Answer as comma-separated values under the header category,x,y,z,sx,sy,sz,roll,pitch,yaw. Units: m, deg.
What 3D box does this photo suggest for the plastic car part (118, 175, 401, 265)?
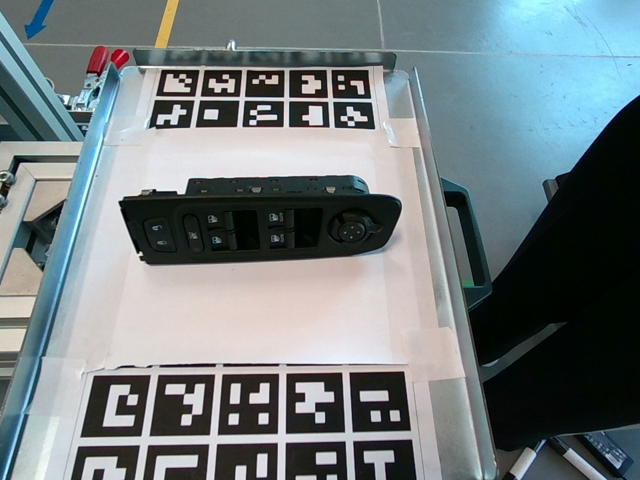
category,x,y,z,sx,sy,sz,roll,pitch,yaw
plastic car part,-0.041,-0.020,0.340,0.203,0.067,0.067,1,35,0
